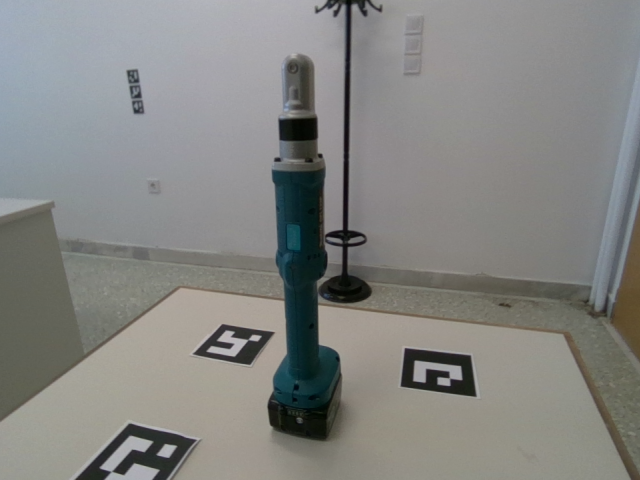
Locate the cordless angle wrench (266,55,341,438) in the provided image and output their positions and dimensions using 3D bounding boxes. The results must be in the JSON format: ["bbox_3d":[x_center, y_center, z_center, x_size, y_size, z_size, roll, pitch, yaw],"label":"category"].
[{"bbox_3d":[-0.020,0.022,0.478,0.075,0.423,0.097,4,19,16],"label":"cordless angle wrench"}]
